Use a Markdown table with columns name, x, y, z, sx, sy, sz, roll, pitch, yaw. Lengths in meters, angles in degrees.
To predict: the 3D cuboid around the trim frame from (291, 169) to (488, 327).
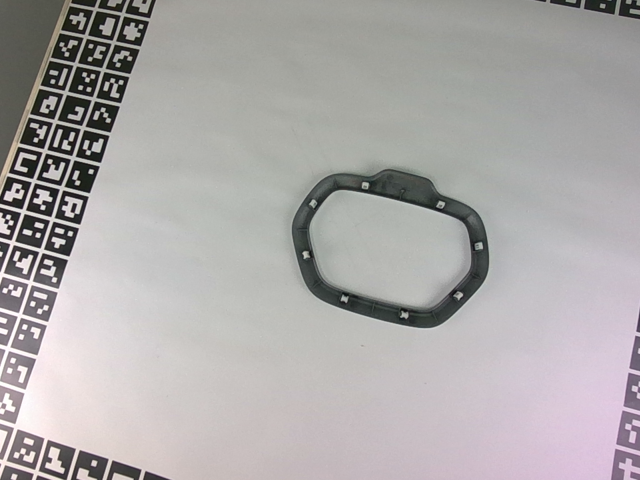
| name | x | y | z | sx | sy | sz | roll | pitch | yaw |
| --- | --- | --- | --- | --- | --- | --- | --- | --- | --- |
| trim frame | 0.081 | 0.003 | 0.529 | 0.249 | 0.184 | 0.027 | 17 | -10 | 14 |
